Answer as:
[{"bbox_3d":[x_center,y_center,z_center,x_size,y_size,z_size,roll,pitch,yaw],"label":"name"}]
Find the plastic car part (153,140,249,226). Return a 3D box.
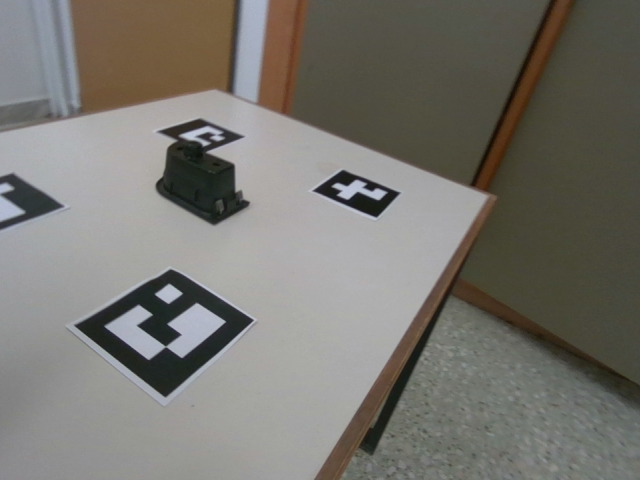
[{"bbox_3d":[-0.145,-0.078,0.498,0.117,0.071,0.065,29,35,16],"label":"plastic car part"}]
